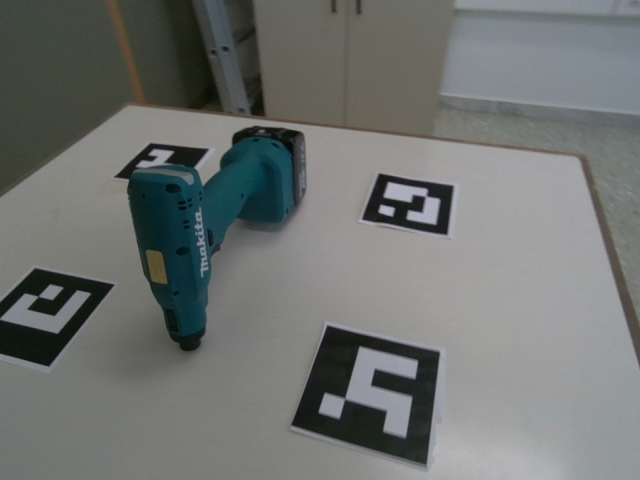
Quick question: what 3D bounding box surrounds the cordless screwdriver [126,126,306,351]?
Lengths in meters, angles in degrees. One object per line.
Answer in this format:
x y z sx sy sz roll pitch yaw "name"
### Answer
-0.086 -0.021 0.426 0.075 0.159 0.247 7 27 15 "cordless screwdriver"
